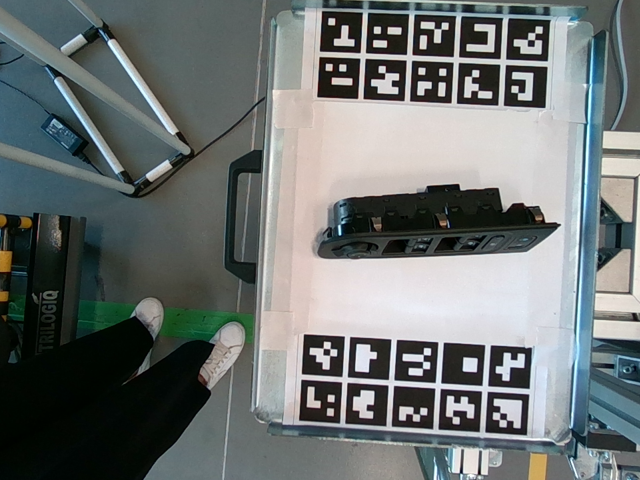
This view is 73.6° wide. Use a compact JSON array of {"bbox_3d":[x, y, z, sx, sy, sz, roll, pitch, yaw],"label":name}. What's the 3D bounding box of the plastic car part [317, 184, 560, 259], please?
[{"bbox_3d":[0.096,-0.016,0.386,0.203,0.067,0.066,-7,-13,2],"label":"plastic car part"}]
